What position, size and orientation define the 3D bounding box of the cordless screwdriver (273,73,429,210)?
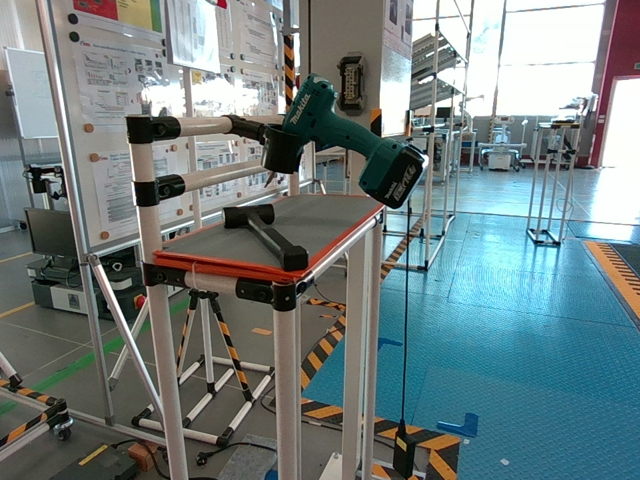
[{"bbox_3d":[0.043,-0.138,0.695,0.249,0.159,0.074,38,26,8],"label":"cordless screwdriver"}]
